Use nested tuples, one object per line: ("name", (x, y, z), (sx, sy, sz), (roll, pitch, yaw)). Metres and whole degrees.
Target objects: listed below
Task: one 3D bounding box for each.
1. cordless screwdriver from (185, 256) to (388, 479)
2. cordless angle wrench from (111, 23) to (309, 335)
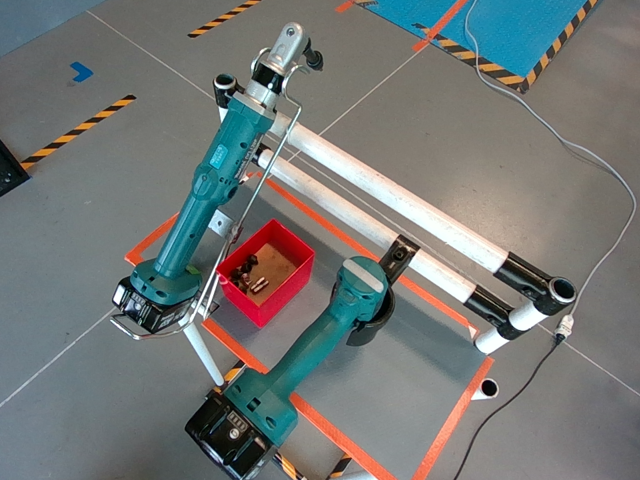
("cordless screwdriver", (-0.019, 0.137, 0.465), (0.074, 0.248, 0.159), (38, -18, 18))
("cordless angle wrench", (-0.130, -0.073, 0.537), (0.074, 0.423, 0.098), (34, 13, 12))
